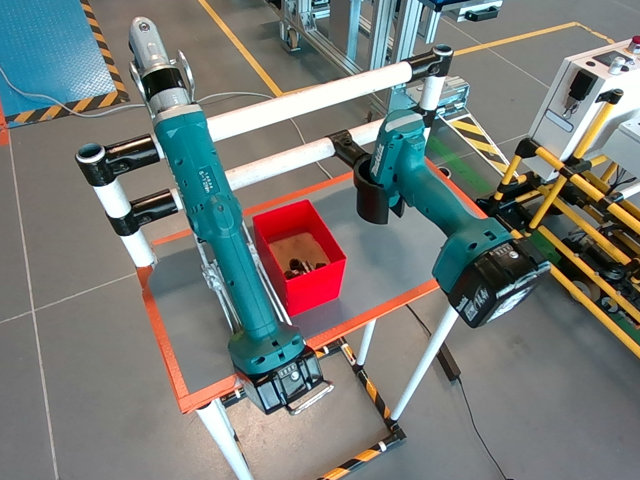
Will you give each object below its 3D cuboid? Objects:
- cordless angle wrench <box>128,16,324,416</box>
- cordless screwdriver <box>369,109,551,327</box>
[{"bbox_3d":[-0.111,-0.025,0.452,0.074,0.423,0.098,-23,8,-24],"label":"cordless angle wrench"},{"bbox_3d":[0.136,-0.018,0.502,0.074,0.248,0.160,-22,-27,-18],"label":"cordless screwdriver"}]
